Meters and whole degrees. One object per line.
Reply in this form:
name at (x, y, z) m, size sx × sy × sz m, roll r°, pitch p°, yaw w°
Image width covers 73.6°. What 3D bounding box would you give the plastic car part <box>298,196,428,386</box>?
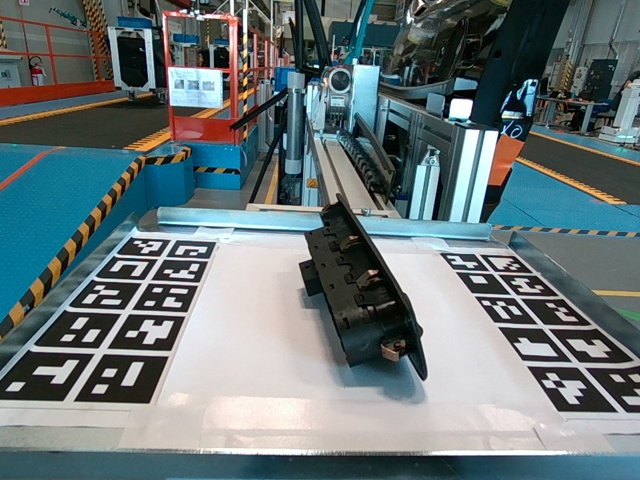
plastic car part at (0.021, 0.027, 0.317) m, size 0.067 × 0.066 × 0.203 m, roll -11°, pitch 23°, yaw -9°
